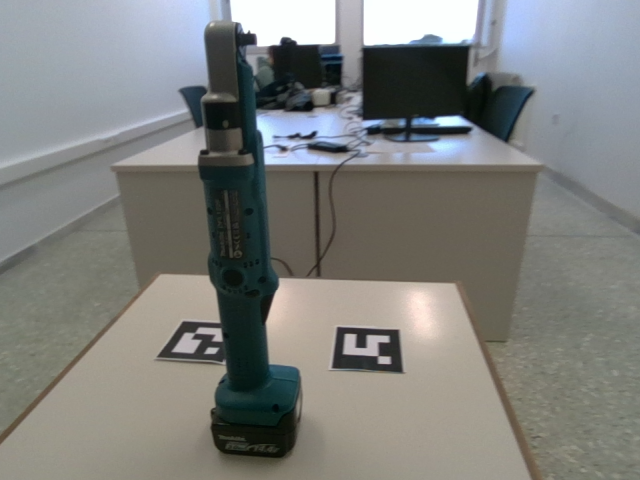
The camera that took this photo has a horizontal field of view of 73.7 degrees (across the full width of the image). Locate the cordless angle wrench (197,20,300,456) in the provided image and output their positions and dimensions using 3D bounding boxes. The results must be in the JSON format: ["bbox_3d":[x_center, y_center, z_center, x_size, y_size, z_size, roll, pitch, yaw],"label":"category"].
[{"bbox_3d":[-0.076,0.025,0.413,0.098,0.423,0.074,1,23,4],"label":"cordless angle wrench"}]
